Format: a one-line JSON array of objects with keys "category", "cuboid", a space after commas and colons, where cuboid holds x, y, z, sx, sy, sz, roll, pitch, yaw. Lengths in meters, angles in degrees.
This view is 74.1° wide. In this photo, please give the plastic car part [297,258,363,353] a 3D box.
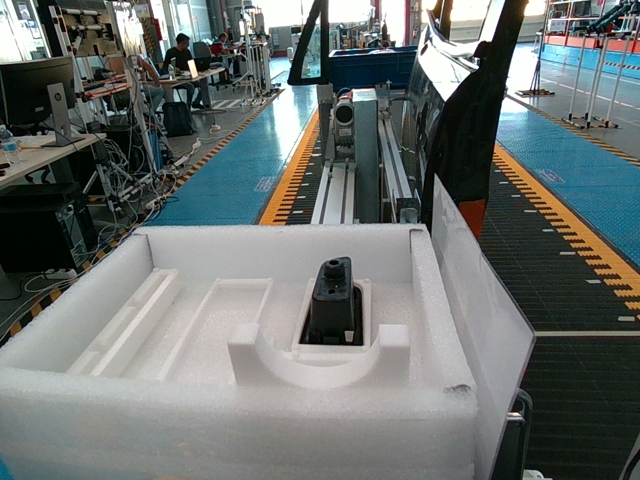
[{"category": "plastic car part", "cuboid": [0.015, 0.059, 0.460, 0.066, 0.071, 0.116, 1, 30, 8]}]
